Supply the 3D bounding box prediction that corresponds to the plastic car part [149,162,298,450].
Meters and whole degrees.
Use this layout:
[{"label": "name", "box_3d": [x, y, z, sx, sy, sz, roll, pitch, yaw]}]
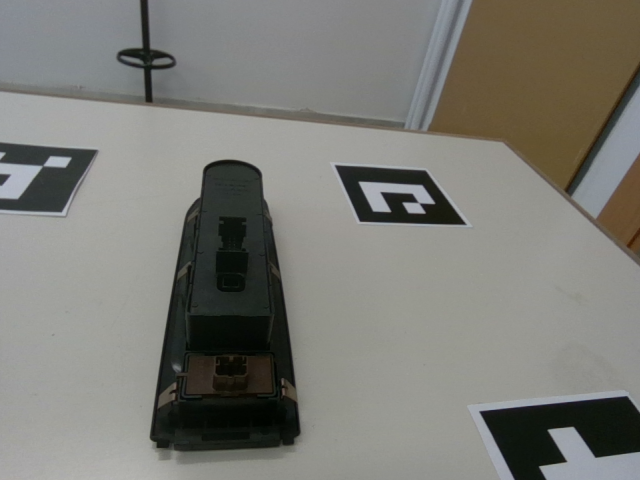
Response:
[{"label": "plastic car part", "box_3d": [-0.057, 0.012, 0.255, 0.066, 0.067, 0.203, -3, 35, -9]}]
